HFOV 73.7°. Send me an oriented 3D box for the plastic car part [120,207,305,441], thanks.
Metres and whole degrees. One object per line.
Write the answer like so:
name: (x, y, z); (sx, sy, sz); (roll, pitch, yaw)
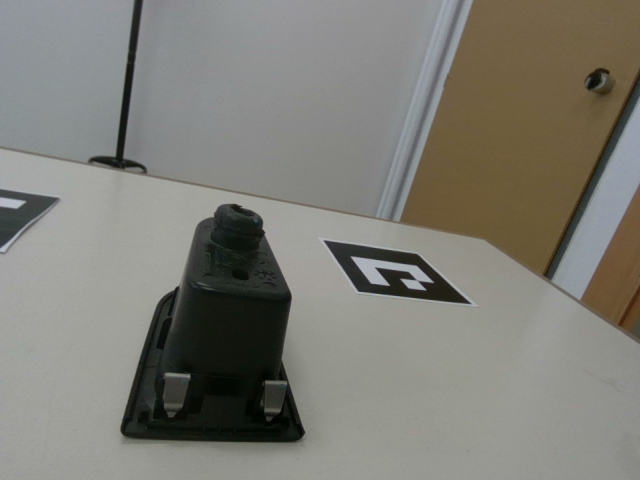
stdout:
plastic car part: (-0.043, 0.023, 0.196); (0.065, 0.071, 0.117); (9, 22, -17)
